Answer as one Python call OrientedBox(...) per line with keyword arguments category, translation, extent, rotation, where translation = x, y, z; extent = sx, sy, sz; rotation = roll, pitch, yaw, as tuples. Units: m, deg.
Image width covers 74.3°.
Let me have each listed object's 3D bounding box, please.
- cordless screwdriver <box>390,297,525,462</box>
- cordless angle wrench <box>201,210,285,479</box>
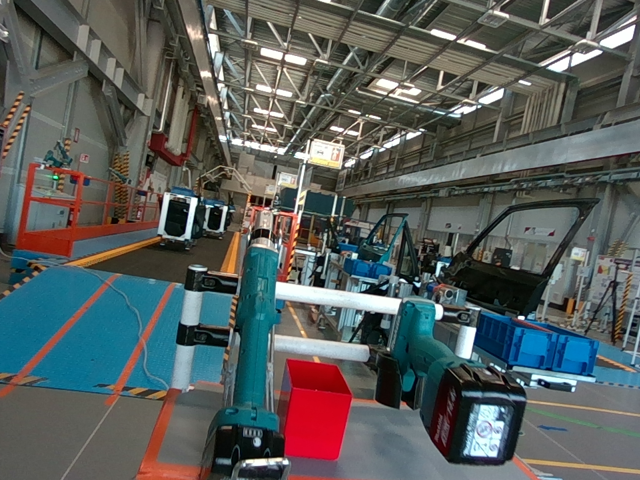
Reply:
OrientedBox(category="cordless screwdriver", translation=(0.145, 0.187, 0.542), extent=(0.074, 0.159, 0.248), rotation=(9, 11, -10))
OrientedBox(category="cordless angle wrench", translation=(-0.092, 0.108, 0.600), extent=(0.074, 0.421, 0.098), rotation=(15, -45, -18))
